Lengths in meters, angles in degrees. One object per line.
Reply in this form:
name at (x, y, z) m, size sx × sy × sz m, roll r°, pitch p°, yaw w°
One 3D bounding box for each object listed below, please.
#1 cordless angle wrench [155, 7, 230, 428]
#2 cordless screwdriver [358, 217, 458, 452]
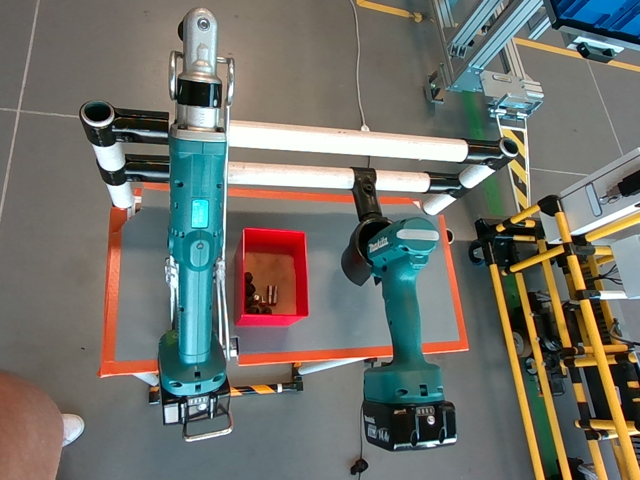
cordless angle wrench at (-0.129, -0.002, 0.435) m, size 0.074 × 0.424 × 0.098 m, roll -2°, pitch 22°, yaw -26°
cordless screwdriver at (0.086, 0.108, 0.504) m, size 0.074 × 0.248 × 0.159 m, roll 3°, pitch -13°, yaw -16°
